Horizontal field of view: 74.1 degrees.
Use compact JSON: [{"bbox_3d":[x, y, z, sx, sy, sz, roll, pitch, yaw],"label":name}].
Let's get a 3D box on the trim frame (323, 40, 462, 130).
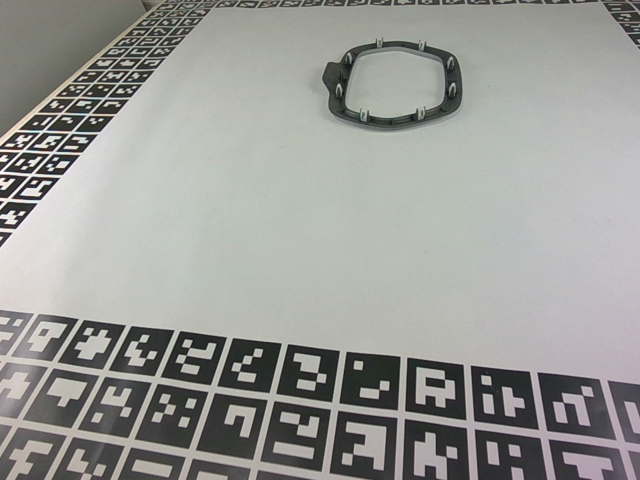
[{"bbox_3d":[0.098,-0.221,0.582,0.185,0.247,0.027,5,-41,12],"label":"trim frame"}]
